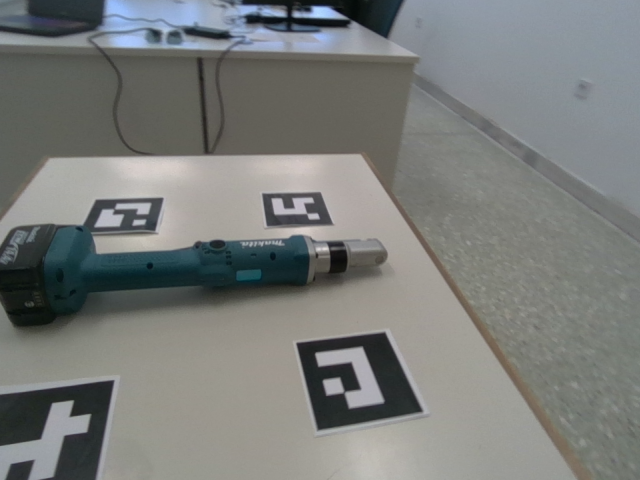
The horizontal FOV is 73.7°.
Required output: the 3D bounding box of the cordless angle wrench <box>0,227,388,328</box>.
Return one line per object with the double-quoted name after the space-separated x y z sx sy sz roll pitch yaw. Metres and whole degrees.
-0.120 0.027 0.494 0.421 0.074 0.098 -3 33 -13 "cordless angle wrench"
